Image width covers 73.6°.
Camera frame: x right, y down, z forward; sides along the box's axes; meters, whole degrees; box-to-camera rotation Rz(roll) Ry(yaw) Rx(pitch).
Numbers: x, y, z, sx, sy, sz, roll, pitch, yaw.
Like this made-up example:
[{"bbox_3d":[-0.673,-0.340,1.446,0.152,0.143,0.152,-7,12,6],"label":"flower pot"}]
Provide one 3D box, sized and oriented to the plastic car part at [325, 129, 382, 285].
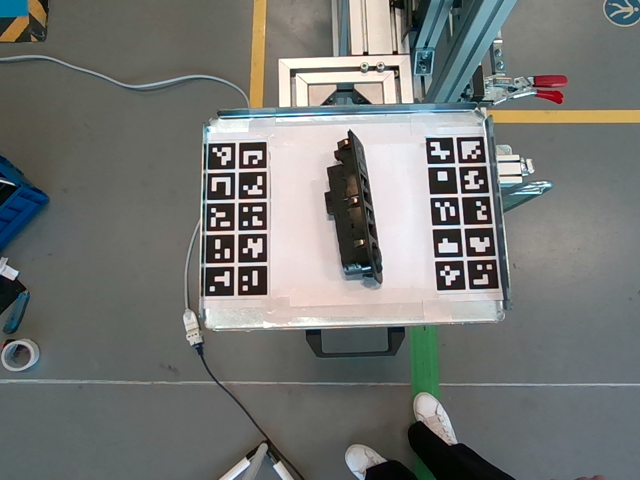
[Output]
[{"bbox_3d":[0.043,-0.038,0.569,0.067,0.202,0.066,-14,-11,11],"label":"plastic car part"}]
